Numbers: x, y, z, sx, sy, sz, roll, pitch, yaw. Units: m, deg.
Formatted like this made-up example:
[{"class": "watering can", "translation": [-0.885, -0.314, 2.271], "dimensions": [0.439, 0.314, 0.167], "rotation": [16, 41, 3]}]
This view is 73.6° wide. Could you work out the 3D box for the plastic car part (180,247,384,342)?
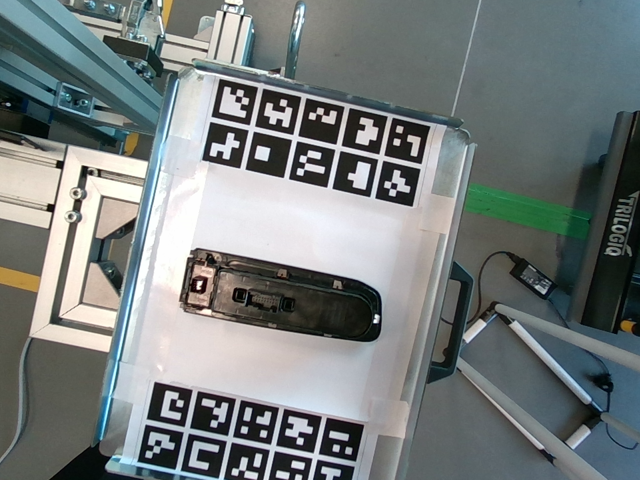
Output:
[{"class": "plastic car part", "translation": [-0.033, 0.056, 0.407], "dimensions": [0.203, 0.066, 0.067], "rotation": [11, -6, -4]}]
